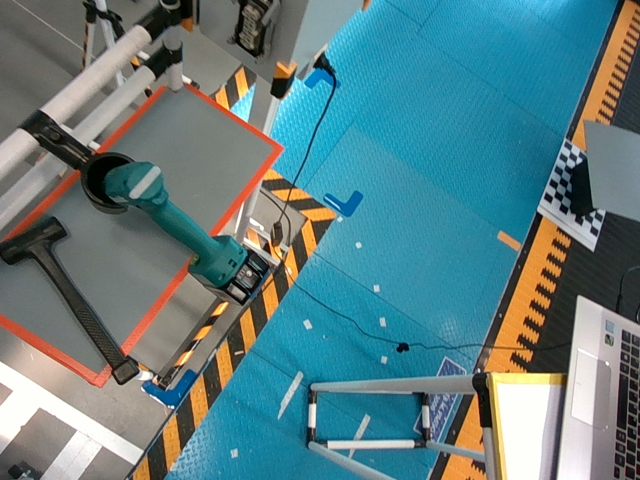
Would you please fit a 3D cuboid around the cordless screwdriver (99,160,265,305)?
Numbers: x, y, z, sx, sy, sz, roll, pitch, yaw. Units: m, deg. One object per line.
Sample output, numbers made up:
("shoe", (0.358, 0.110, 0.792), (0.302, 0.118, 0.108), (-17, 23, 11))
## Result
("cordless screwdriver", (-0.205, -0.010, 0.611), (0.160, 0.074, 0.248), (4, -37, 51))
